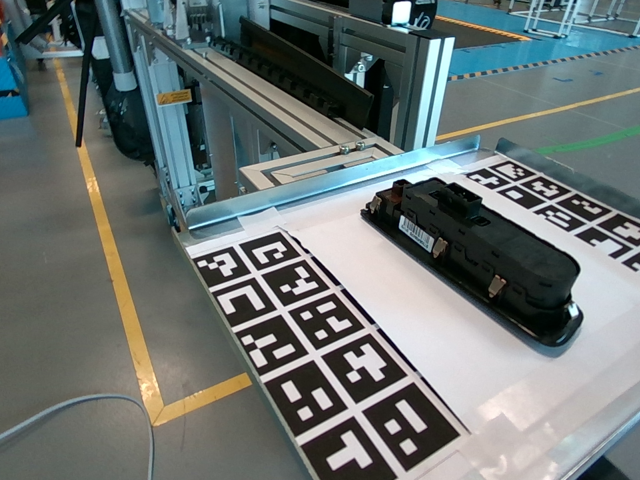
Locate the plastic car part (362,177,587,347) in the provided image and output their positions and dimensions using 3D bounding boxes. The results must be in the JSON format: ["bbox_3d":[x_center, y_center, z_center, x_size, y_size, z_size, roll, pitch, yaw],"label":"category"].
[{"bbox_3d":[0.123,-0.002,0.345,0.066,0.067,0.203,-14,43,-31],"label":"plastic car part"}]
